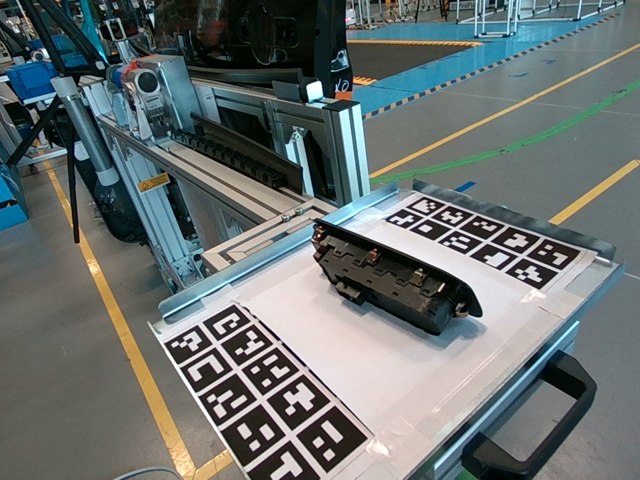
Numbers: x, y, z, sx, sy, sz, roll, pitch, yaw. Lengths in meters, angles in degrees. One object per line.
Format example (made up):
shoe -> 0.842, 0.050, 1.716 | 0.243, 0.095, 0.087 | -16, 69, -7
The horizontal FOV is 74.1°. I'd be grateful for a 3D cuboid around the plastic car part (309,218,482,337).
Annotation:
plastic car part -> 0.060, 0.039, 0.433 | 0.204, 0.066, 0.067 | 20, 54, 37
